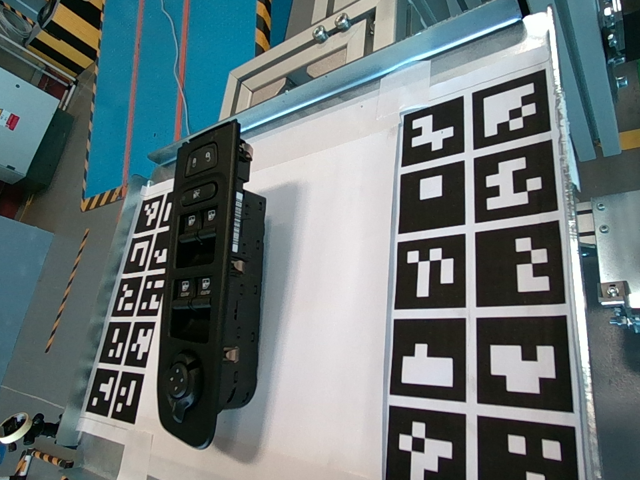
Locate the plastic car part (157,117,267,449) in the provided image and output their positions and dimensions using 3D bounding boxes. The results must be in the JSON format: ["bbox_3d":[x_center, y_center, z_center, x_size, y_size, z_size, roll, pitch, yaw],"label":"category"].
[{"bbox_3d":[-0.070,0.027,0.290,0.067,0.202,0.067,-6,-19,29],"label":"plastic car part"}]
